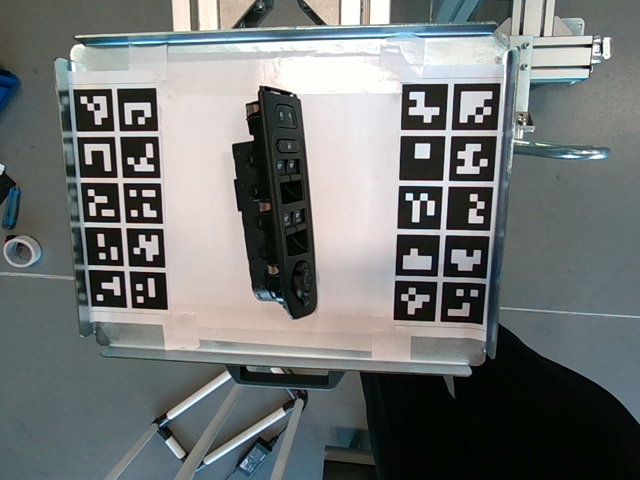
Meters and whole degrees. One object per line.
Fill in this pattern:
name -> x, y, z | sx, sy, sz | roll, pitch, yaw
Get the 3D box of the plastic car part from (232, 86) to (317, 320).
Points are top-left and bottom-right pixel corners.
plastic car part -> -0.043, -0.025, 0.382 | 0.067, 0.203, 0.066 | -7, 7, 20
